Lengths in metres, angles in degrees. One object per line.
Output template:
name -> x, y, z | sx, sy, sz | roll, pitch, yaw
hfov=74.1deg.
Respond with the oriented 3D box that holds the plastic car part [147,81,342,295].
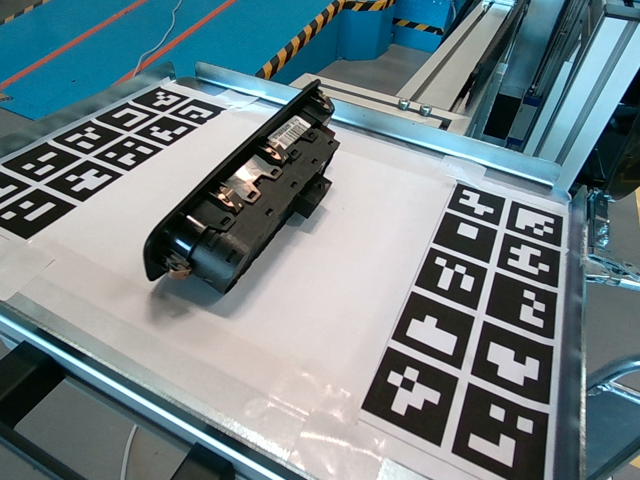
plastic car part -> -0.035, -0.033, 0.289 | 0.067, 0.068, 0.202 | -46, 3, 46
